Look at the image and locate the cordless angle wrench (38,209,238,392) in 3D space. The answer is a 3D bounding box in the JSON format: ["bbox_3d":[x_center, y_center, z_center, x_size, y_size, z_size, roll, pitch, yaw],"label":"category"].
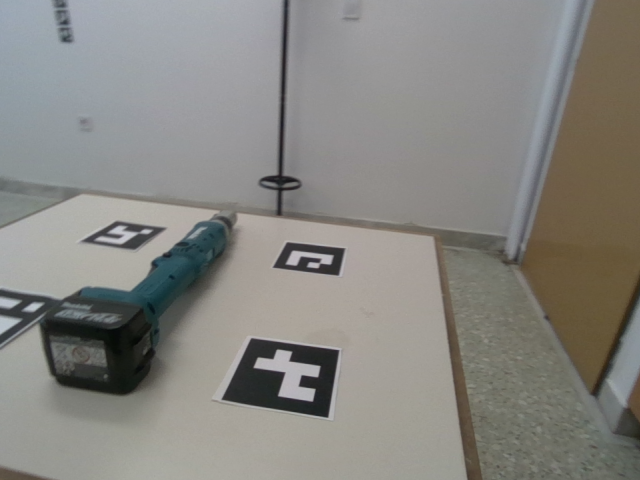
[{"bbox_3d":[-0.189,0.031,0.582,0.098,0.074,0.421,6,22,6],"label":"cordless angle wrench"}]
